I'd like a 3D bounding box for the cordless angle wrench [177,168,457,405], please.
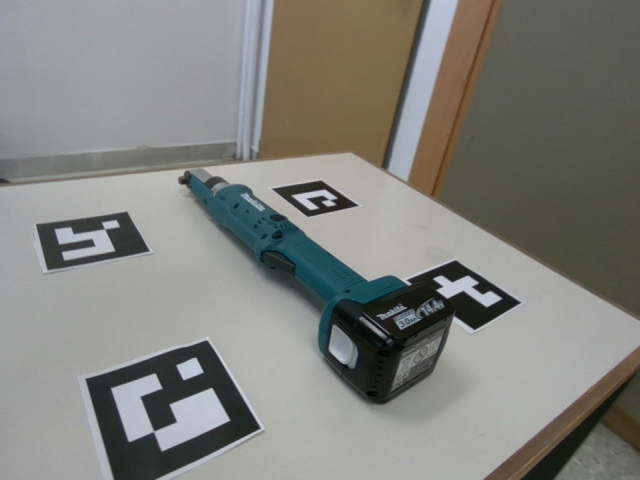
[{"bbox_3d":[-0.051,0.000,0.478,0.097,0.074,0.427,-15,36,-37],"label":"cordless angle wrench"}]
